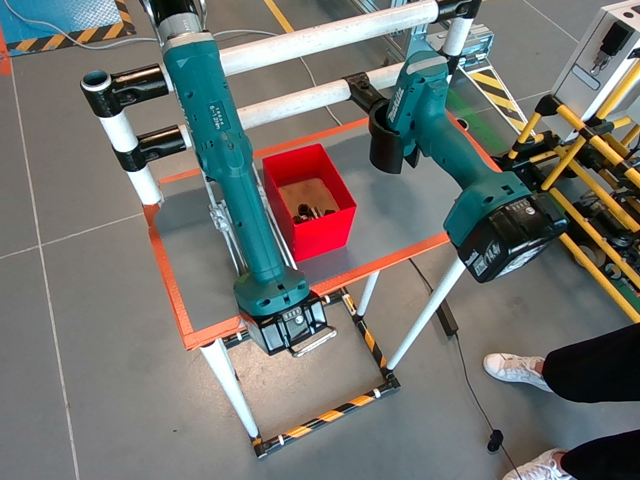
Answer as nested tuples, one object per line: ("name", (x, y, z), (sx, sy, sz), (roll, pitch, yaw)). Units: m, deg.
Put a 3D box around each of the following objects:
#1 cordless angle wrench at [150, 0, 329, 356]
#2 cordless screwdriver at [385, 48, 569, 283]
("cordless angle wrench", (-0.097, -0.090, 0.438), (0.074, 0.423, 0.098), (-22, 12, -18))
("cordless screwdriver", (0.148, -0.073, 0.483), (0.074, 0.248, 0.159), (-22, -20, -14))
